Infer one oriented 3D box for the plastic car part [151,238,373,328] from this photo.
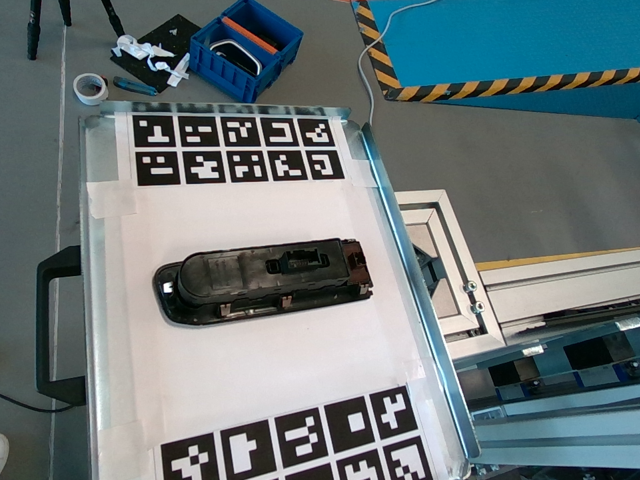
[{"bbox_3d":[-0.041,0.033,0.380,0.202,0.066,0.067,-8,-16,-20],"label":"plastic car part"}]
